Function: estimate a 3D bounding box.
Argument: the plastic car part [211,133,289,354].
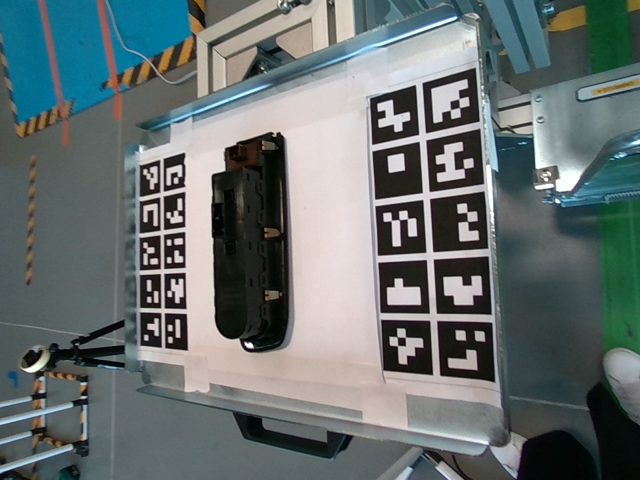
[{"bbox_3d":[-0.065,0.003,0.382,0.067,0.203,0.067,-6,-4,27],"label":"plastic car part"}]
